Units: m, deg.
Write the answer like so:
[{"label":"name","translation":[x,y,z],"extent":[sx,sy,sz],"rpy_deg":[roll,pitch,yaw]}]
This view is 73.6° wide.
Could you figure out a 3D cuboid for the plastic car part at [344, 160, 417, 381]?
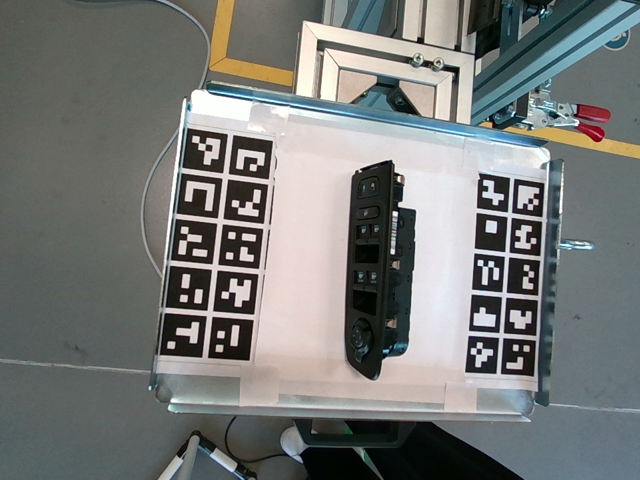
[{"label":"plastic car part","translation":[0.061,0.031,0.422],"extent":[0.067,0.203,0.067],"rpy_deg":[11,-7,-37]}]
